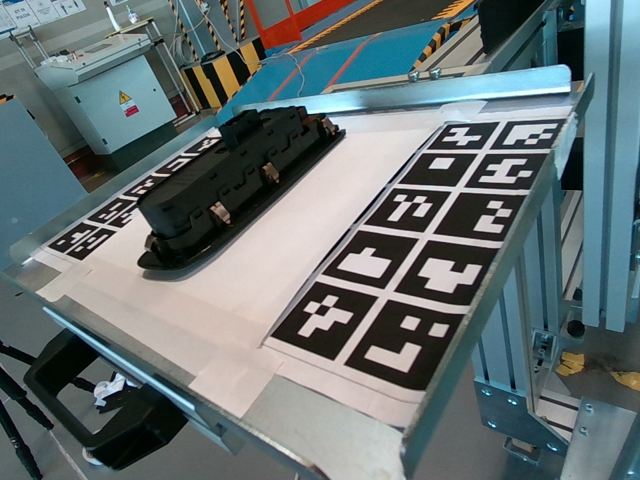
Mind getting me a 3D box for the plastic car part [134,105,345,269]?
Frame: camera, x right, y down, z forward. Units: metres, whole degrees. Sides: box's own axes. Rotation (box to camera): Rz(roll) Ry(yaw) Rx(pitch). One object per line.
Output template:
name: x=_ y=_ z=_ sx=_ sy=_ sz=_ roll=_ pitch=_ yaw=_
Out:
plastic car part: x=-0.061 y=-0.055 z=0.325 sx=0.067 sy=0.067 sz=0.202 roll=13 pitch=50 yaw=34
